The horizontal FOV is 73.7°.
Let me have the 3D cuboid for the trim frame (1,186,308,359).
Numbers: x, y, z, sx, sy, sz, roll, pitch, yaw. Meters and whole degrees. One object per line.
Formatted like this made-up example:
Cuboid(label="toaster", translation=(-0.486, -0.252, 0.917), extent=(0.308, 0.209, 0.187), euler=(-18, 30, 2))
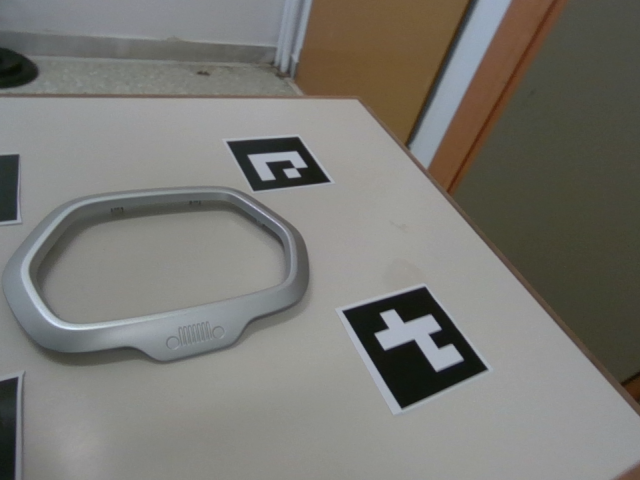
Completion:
Cuboid(label="trim frame", translation=(-0.129, 0.016, 0.373), extent=(0.246, 0.027, 0.185), euler=(-10, 47, -27))
